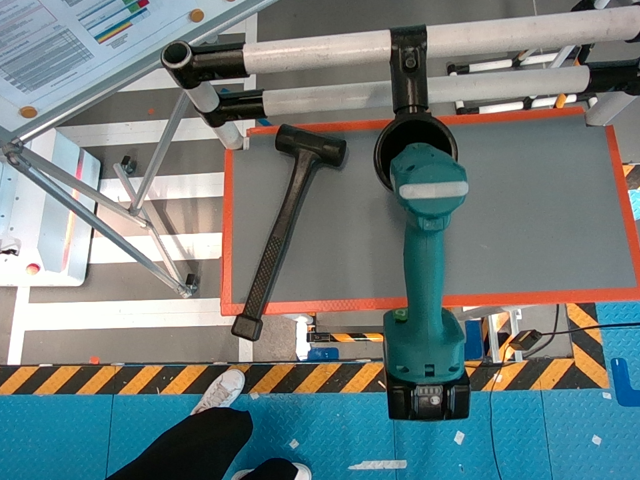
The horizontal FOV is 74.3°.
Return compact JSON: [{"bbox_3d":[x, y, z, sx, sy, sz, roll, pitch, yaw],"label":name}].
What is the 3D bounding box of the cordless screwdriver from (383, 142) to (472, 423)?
[{"bbox_3d":[0.095,0.034,0.403,0.074,0.249,0.159,-2,18,7],"label":"cordless screwdriver"}]
